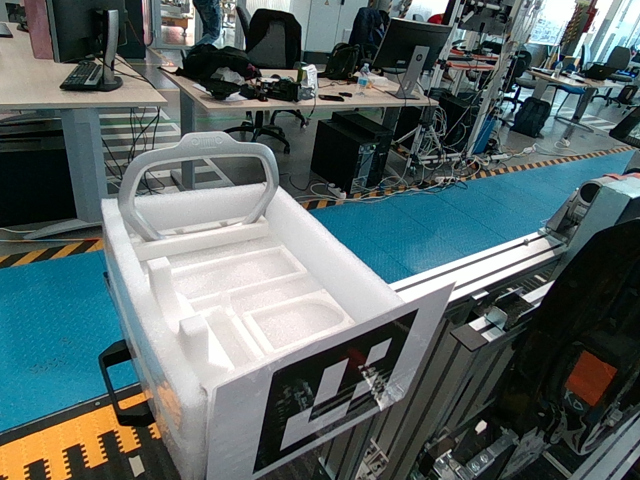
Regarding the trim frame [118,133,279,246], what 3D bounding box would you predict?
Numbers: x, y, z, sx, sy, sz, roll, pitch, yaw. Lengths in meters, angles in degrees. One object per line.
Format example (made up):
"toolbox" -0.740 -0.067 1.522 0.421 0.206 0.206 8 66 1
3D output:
"trim frame" -0.172 -0.073 0.640 0.247 0.185 0.027 -12 46 -29
